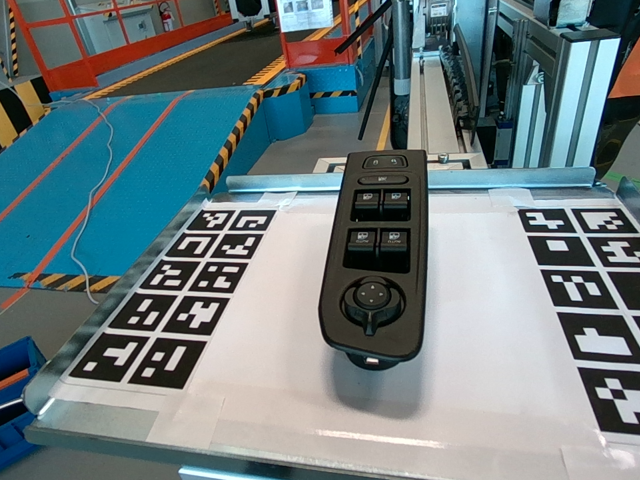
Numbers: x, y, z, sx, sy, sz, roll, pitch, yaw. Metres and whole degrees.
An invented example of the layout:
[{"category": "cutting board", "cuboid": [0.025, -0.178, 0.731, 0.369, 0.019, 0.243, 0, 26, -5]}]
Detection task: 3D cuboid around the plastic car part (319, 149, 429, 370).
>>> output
[{"category": "plastic car part", "cuboid": [0.041, 0.007, 0.304, 0.066, 0.067, 0.202, 6, 39, 7]}]
